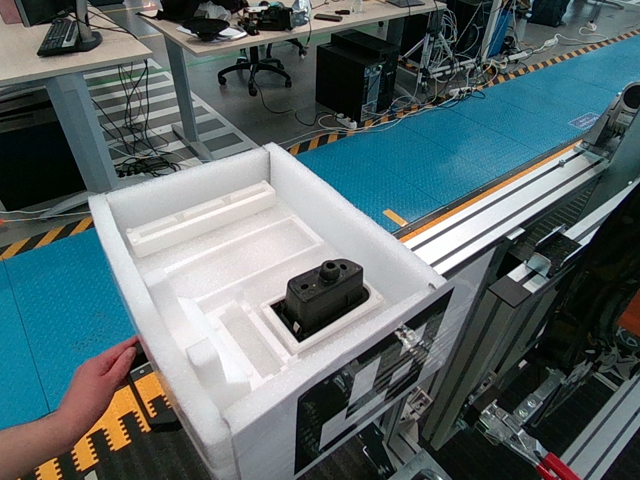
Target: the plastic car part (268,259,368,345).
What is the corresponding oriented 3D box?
[{"bbox_3d":[0.004,0.058,0.499,0.116,0.071,0.066,-26,50,-25],"label":"plastic car part"}]
